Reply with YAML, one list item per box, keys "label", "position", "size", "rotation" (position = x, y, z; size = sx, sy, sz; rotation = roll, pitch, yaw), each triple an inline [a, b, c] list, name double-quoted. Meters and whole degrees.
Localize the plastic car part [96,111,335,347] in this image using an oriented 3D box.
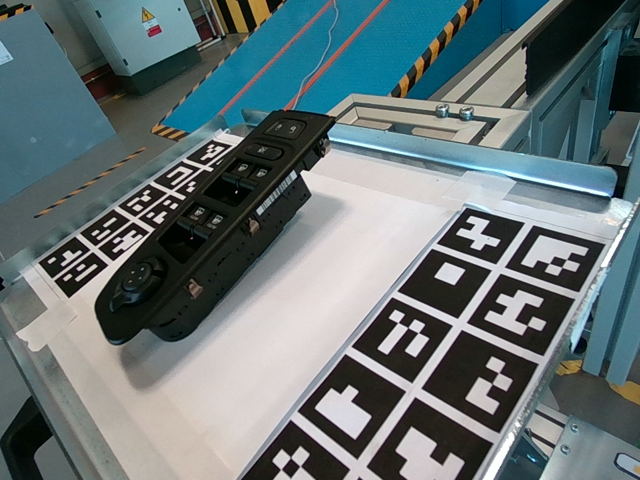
- label: "plastic car part"
  position: [-0.066, -0.008, 0.298]
  size: [0.066, 0.202, 0.067]
  rotation: [27, -27, 32]
